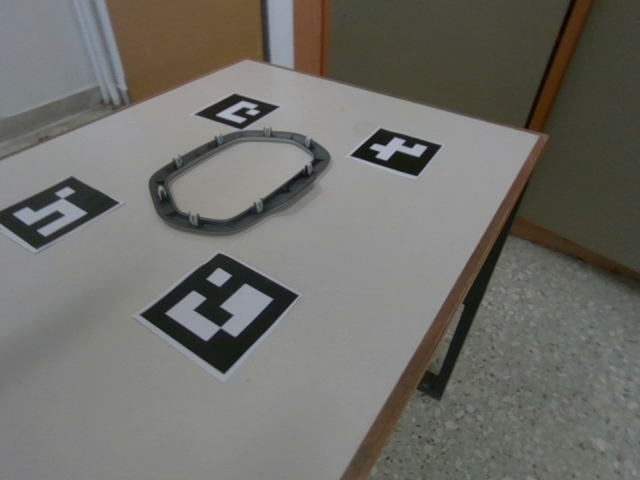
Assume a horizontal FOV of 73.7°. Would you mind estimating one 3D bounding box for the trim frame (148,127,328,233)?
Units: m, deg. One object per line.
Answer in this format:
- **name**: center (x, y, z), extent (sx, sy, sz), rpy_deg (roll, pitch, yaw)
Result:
- **trim frame**: center (-0.098, -0.087, 0.539), extent (0.185, 0.027, 0.246), rpy_deg (25, 45, 25)
